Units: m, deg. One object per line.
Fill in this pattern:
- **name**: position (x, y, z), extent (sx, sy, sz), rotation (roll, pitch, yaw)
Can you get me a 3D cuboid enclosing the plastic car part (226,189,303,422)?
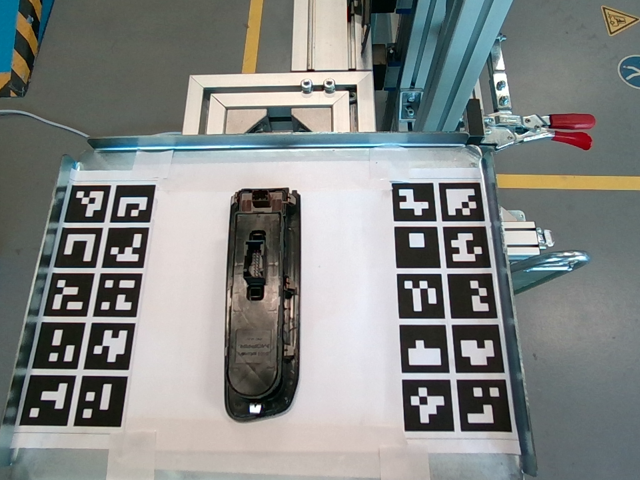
- **plastic car part**: position (-0.046, 0.043, 0.352), extent (0.066, 0.202, 0.067), rotation (0, -17, -5)
